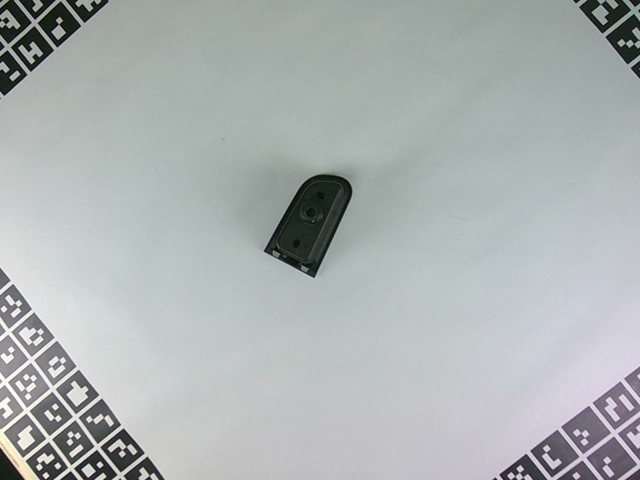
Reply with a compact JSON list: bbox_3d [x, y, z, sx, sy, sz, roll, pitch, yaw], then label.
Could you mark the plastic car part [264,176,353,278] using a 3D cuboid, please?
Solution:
[{"bbox_3d":[-0.011,-0.022,0.461,0.066,0.116,0.071,28,5,3],"label":"plastic car part"}]
